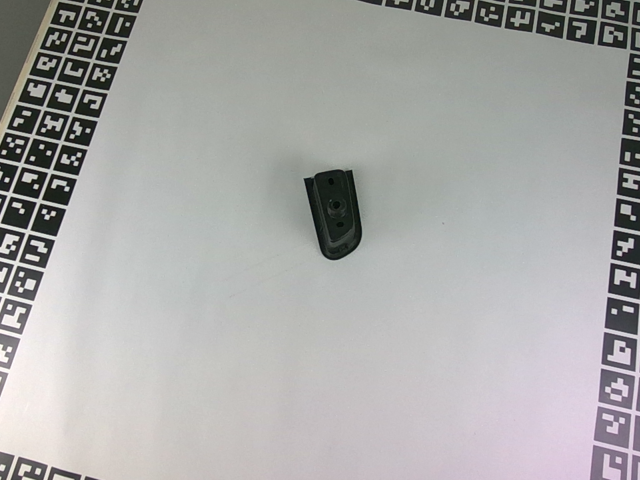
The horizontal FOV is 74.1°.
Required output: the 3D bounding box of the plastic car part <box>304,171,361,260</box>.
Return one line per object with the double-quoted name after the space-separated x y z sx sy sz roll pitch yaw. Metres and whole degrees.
0.019 -0.040 0.538 0.066 0.116 0.071 -10 -16 0 "plastic car part"
